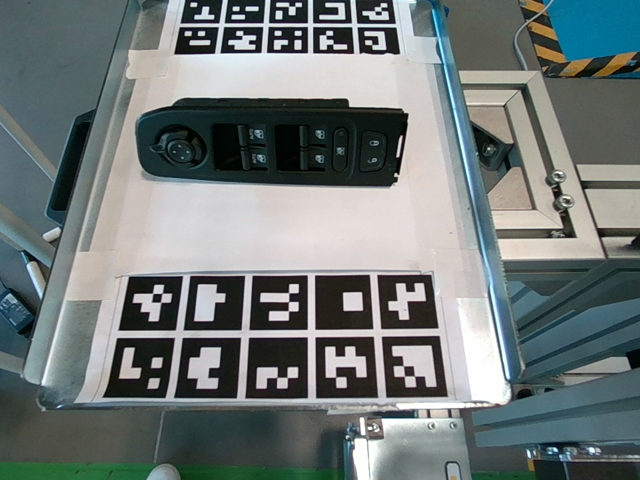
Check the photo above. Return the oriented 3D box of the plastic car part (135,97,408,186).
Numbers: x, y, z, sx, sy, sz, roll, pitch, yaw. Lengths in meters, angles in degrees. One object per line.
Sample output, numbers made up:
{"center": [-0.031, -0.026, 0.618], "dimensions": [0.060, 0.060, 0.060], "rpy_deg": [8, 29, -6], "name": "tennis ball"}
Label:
{"center": [-0.040, -0.084, 0.333], "dimensions": [0.203, 0.067, 0.066], "rpy_deg": [-2, -39, -2], "name": "plastic car part"}
